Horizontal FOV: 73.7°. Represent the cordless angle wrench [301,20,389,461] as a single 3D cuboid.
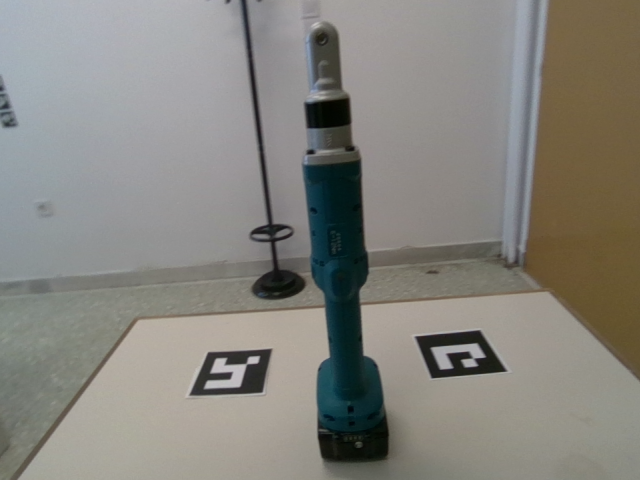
[{"bbox_3d":[0.018,0.024,0.412,0.074,0.422,0.098,-4,20,3],"label":"cordless angle wrench"}]
